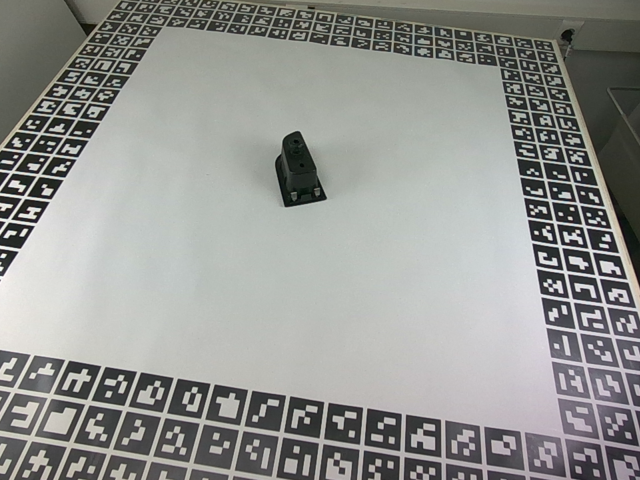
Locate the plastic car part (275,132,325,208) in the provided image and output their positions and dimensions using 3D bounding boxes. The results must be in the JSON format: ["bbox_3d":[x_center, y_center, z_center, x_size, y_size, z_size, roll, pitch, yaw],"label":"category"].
[{"bbox_3d":[-0.036,-0.118,0.656,0.066,0.116,0.071,-11,-30,-11],"label":"plastic car part"}]
